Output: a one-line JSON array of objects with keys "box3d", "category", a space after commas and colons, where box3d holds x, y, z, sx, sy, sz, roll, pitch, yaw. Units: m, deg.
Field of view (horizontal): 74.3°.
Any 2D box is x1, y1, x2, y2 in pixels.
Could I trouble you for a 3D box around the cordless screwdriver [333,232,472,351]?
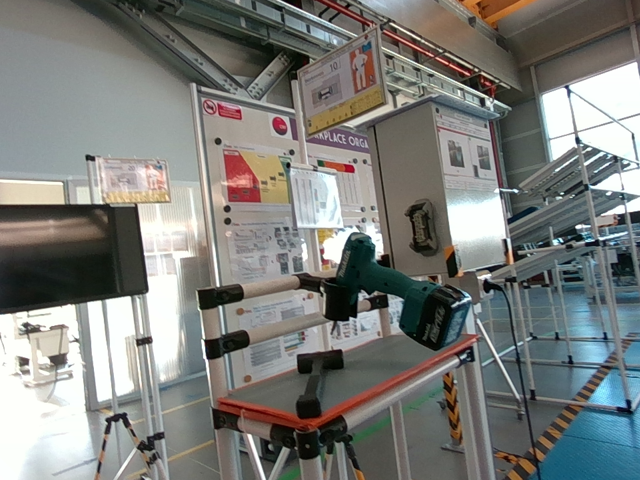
[{"box3d": [0.123, 0.105, 0.737, 0.074, 0.159, 0.248, -7, 29, -46], "category": "cordless screwdriver"}]
